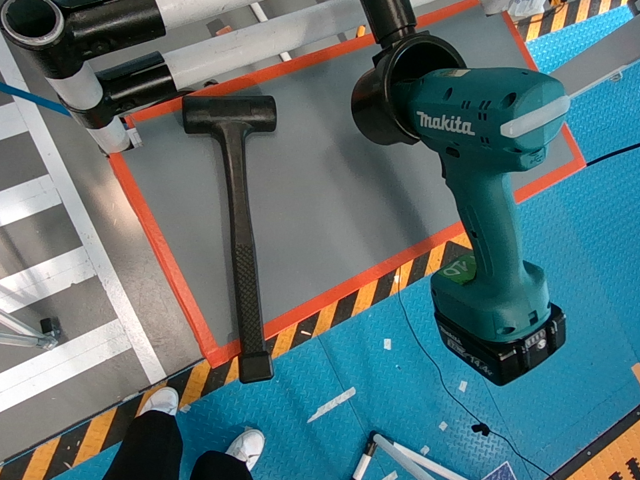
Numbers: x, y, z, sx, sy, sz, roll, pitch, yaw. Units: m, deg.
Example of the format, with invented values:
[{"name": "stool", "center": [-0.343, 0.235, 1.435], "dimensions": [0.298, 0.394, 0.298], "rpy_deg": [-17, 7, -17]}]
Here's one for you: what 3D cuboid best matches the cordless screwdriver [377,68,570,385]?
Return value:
[{"name": "cordless screwdriver", "center": [0.119, -0.014, 0.351], "dimensions": [0.074, 0.249, 0.159], "rpy_deg": [-27, 30, -15]}]
